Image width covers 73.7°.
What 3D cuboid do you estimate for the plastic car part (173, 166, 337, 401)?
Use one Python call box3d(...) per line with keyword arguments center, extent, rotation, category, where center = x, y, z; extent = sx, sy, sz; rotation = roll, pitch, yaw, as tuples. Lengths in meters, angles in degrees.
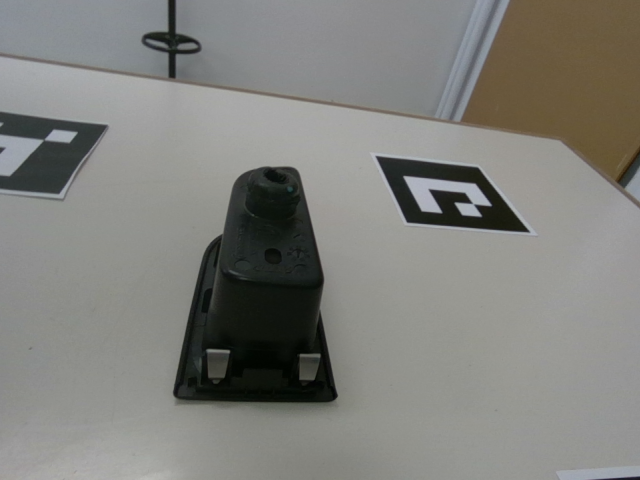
box3d(center=(-0.026, 0.005, 0.199), extent=(0.066, 0.071, 0.117), rotation=(5, 42, -12), category="plastic car part")
